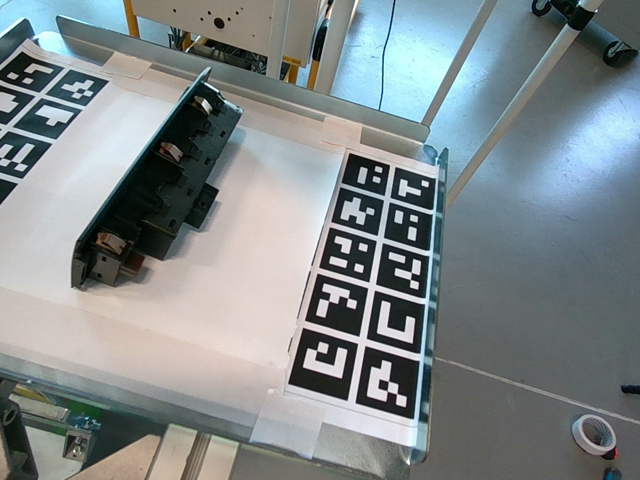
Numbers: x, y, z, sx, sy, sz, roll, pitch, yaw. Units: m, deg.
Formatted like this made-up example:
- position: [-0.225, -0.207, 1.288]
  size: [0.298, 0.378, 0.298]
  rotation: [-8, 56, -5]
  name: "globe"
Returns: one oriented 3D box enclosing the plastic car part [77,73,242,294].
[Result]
- position: [-0.104, -0.051, 0.314]
  size: [0.067, 0.202, 0.066]
  rotation: [17, -38, -10]
  name: "plastic car part"
